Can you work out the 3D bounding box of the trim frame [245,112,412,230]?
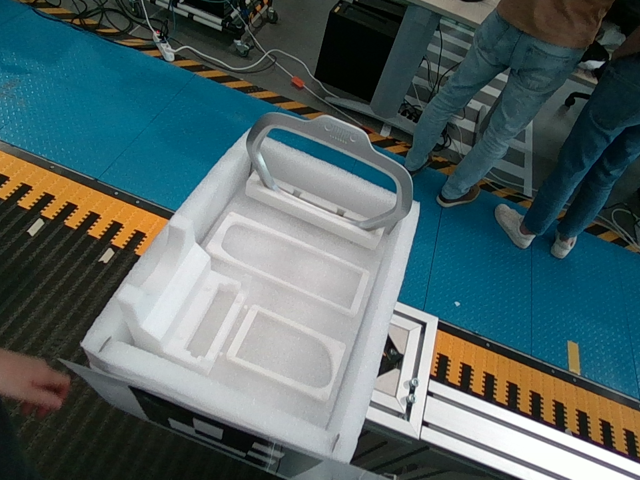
[{"bbox_3d":[0.009,-0.090,0.588,0.249,0.027,0.185,25,-31,4],"label":"trim frame"}]
